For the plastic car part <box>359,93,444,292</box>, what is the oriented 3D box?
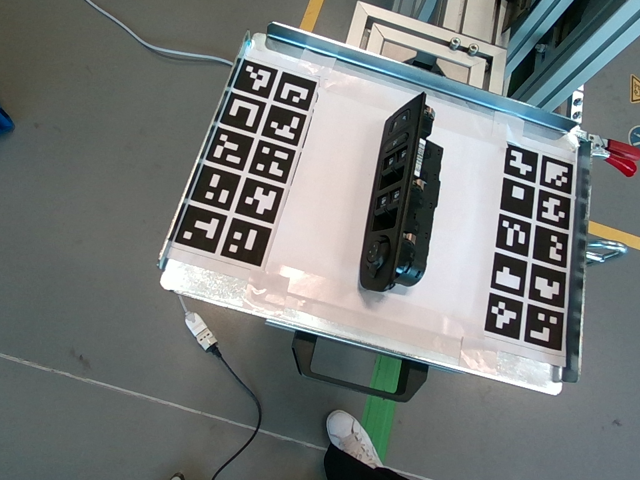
[{"bbox_3d":[0.084,-0.039,0.426,0.067,0.202,0.067,28,-23,-29],"label":"plastic car part"}]
